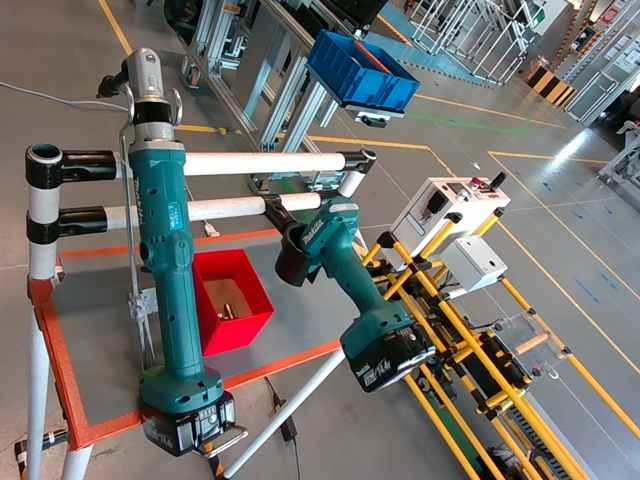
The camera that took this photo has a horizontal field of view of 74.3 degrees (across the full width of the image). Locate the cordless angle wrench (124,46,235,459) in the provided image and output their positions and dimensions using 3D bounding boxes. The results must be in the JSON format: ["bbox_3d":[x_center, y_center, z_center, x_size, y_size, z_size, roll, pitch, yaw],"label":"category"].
[{"bbox_3d":[-0.167,0.010,0.457,0.098,0.423,0.074,-1,6,40],"label":"cordless angle wrench"}]

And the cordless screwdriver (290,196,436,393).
[{"bbox_3d":[0.038,0.081,0.584,0.074,0.248,0.160,-7,-29,-39],"label":"cordless screwdriver"}]
